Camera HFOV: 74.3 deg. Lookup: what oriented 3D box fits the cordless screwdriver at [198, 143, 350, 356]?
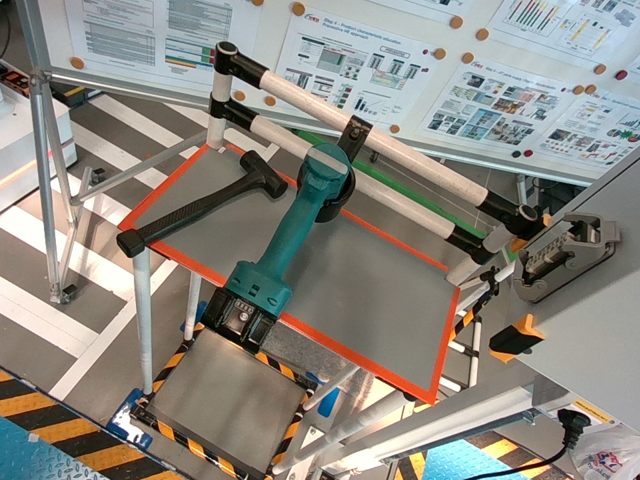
[{"bbox_3d":[-0.043,0.013,0.516,0.074,0.248,0.159,29,-10,3],"label":"cordless screwdriver"}]
